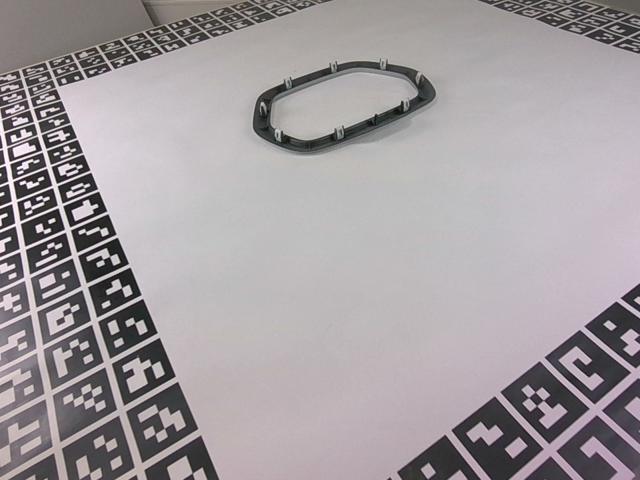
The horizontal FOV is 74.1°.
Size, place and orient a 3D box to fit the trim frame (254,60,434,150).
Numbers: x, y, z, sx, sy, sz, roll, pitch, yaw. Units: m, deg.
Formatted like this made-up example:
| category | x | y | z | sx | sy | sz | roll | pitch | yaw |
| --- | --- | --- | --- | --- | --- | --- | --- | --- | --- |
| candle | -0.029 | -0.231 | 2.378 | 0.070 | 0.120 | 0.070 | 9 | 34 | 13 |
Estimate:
| category | x | y | z | sx | sy | sz | roll | pitch | yaw |
| --- | --- | --- | --- | --- | --- | --- | --- | --- | --- |
| trim frame | 0.029 | -0.185 | 0.553 | 0.247 | 0.027 | 0.184 | -25 | 50 | -20 |
